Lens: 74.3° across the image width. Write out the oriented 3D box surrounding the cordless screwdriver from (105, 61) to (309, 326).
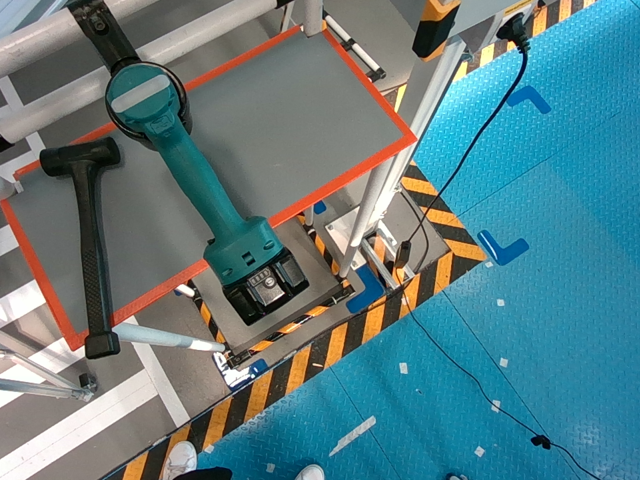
[{"bbox_3d":[-0.111,-0.045,0.423,0.074,0.249,0.159,-32,19,-9],"label":"cordless screwdriver"}]
